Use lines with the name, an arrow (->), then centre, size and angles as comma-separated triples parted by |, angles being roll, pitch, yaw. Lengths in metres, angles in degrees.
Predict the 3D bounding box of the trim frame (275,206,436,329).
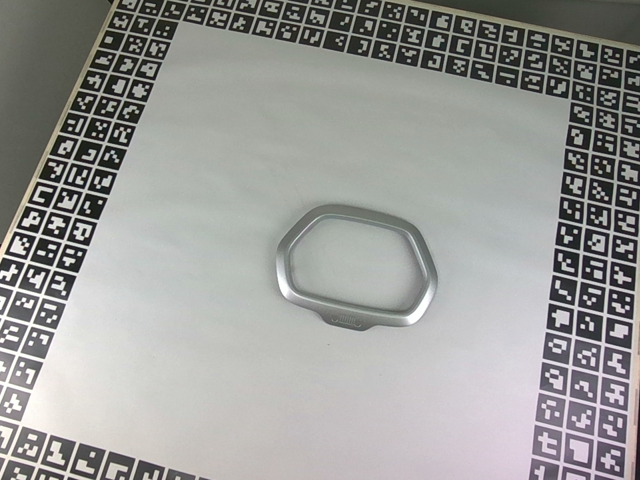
trim frame -> 0.053, 0.041, 0.653 | 0.249, 0.183, 0.027 | 10, -14, 1
